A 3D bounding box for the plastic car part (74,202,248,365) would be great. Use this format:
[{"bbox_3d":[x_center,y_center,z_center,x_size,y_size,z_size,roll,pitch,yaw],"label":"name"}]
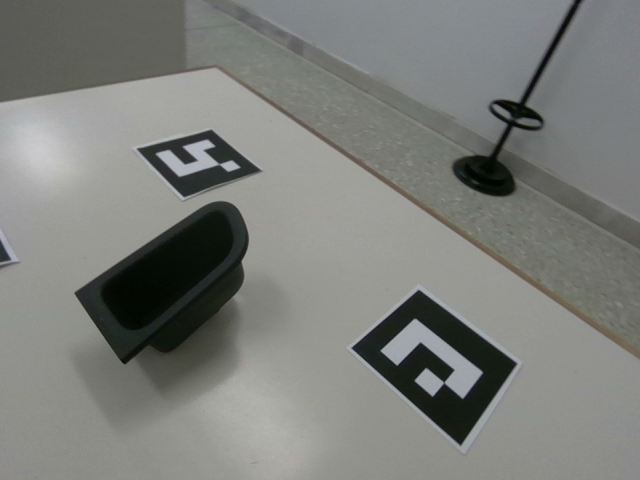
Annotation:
[{"bbox_3d":[-0.097,0.035,0.310,0.116,0.066,0.071,-39,-24,-22],"label":"plastic car part"}]
